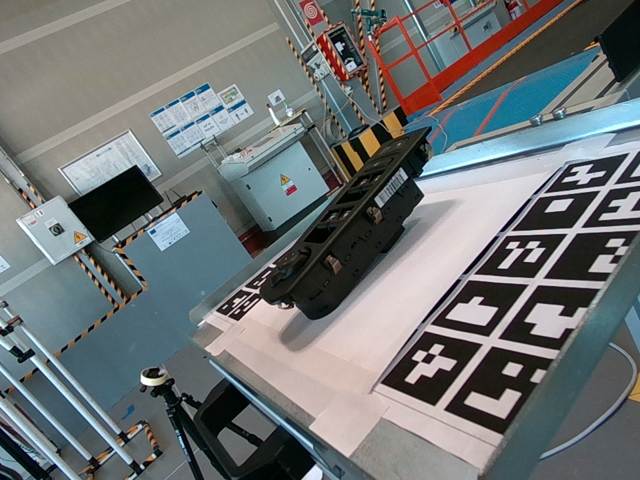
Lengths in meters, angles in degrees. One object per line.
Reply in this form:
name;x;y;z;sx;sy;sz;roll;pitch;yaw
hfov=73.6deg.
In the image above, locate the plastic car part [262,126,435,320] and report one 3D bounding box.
plastic car part;0.031;-0.010;0.361;0.202;0.067;0.067;-45;26;-23
